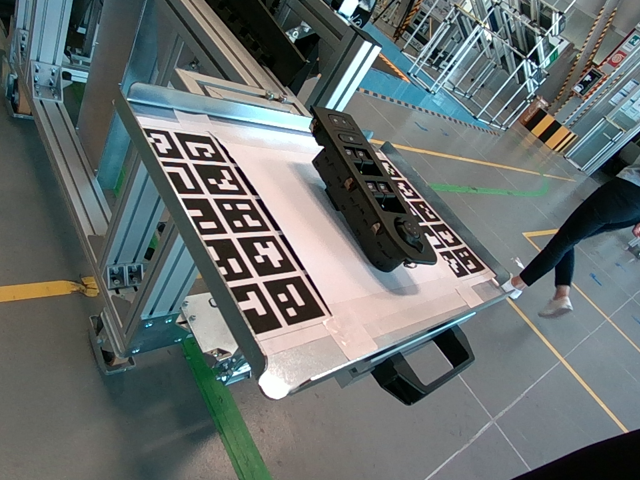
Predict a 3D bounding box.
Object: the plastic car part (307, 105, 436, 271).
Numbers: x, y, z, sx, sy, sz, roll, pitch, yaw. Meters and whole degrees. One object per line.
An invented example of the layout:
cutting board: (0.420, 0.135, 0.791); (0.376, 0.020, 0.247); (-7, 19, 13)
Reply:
plastic car part: (0.042, -0.049, 0.447); (0.067, 0.203, 0.066); (-44, -25, 27)
